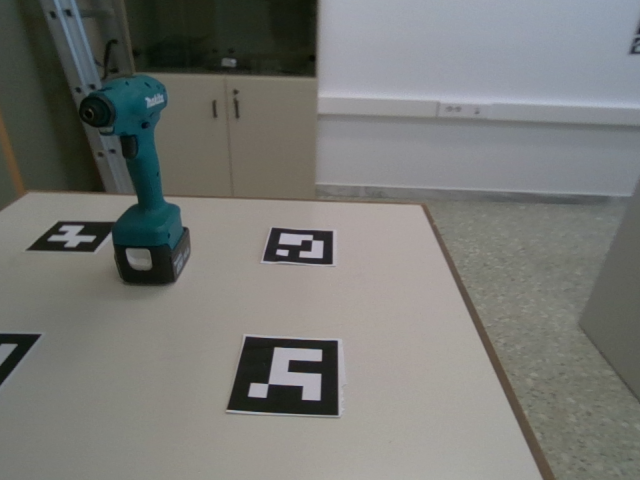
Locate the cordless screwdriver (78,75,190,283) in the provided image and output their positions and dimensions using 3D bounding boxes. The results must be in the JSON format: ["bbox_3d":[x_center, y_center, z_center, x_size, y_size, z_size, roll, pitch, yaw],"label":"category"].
[{"bbox_3d":[-0.219,-0.061,0.511,0.074,0.249,0.159,2,25,1],"label":"cordless screwdriver"}]
